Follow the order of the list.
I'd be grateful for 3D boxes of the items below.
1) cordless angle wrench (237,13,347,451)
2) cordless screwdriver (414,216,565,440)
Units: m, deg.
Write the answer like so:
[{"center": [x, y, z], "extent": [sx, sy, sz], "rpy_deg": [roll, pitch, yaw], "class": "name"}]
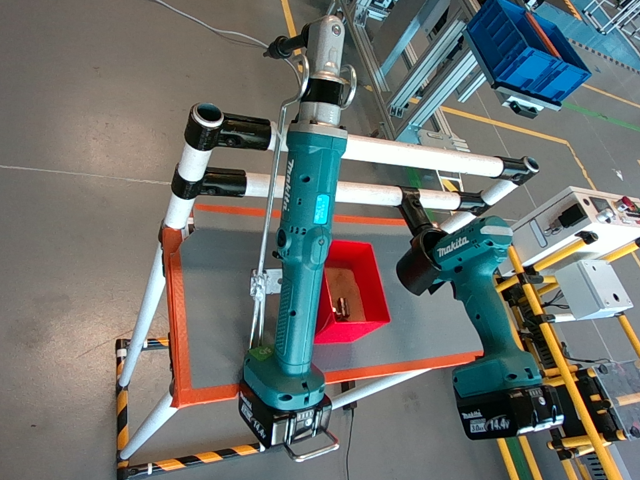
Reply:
[{"center": [-0.018, -0.001, 0.429], "extent": [0.074, 0.423, 0.098], "rpy_deg": [0, 13, -36], "class": "cordless angle wrench"}, {"center": [0.189, 0.110, 0.528], "extent": [0.074, 0.248, 0.160], "rpy_deg": [3, -22, -25], "class": "cordless screwdriver"}]
